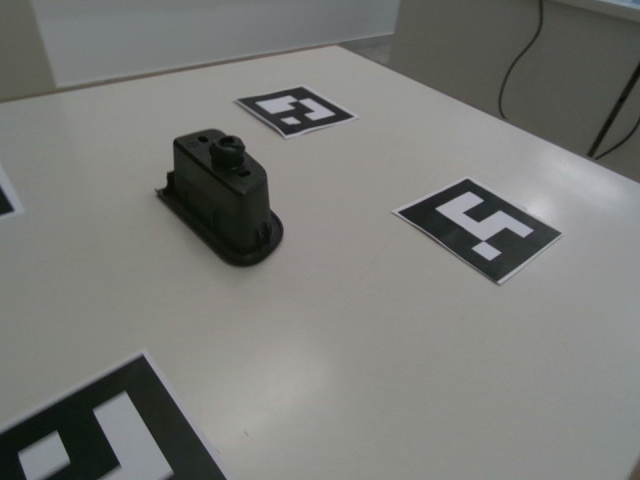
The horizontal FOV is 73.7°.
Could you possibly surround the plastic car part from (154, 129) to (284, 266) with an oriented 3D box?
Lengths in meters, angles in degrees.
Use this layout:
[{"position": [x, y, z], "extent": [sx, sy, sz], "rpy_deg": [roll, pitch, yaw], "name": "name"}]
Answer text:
[{"position": [-0.071, -0.043, 0.314], "extent": [0.065, 0.071, 0.117], "rpy_deg": [-27, 47, -32], "name": "plastic car part"}]
